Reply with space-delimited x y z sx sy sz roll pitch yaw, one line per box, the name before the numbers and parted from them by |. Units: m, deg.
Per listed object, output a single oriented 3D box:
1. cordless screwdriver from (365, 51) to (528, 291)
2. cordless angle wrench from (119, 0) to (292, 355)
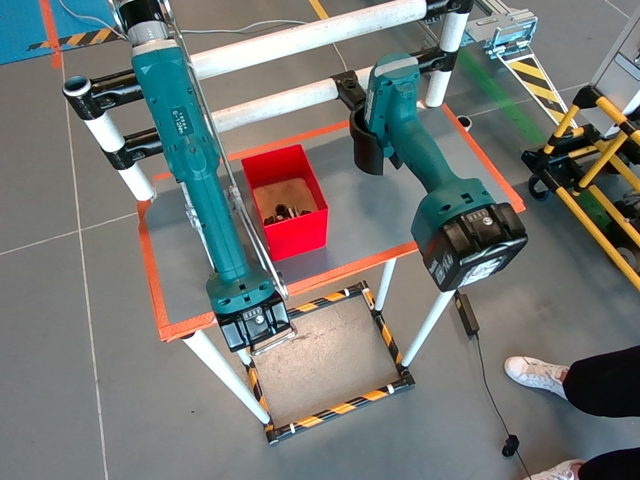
cordless screwdriver | 0.116 -0.067 0.477 0.074 0.248 0.159 -20 -21 -7
cordless angle wrench | -0.135 -0.088 0.451 0.074 0.423 0.098 -20 11 -14
